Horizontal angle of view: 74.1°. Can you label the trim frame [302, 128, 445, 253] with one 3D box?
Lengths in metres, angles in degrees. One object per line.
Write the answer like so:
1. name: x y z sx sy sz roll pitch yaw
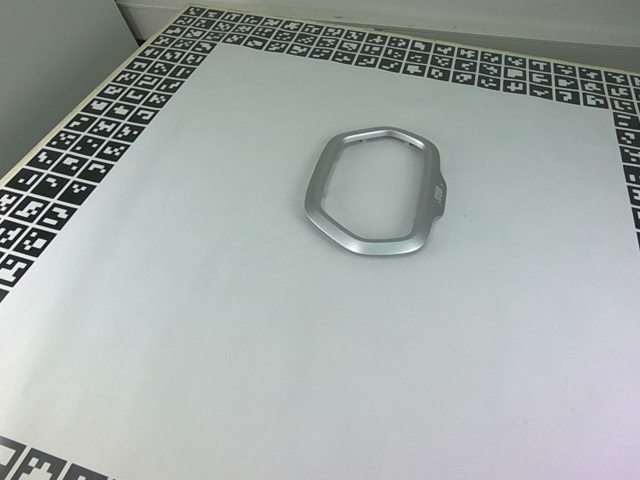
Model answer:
1. trim frame: 0.078 -0.077 0.580 0.185 0.247 0.027 11 -40 10
